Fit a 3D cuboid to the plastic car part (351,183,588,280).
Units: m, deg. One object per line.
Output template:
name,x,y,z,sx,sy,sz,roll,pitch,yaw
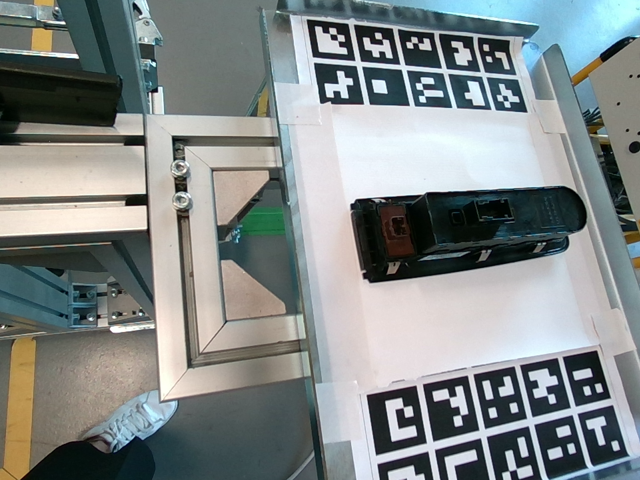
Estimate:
plastic car part,0.131,-0.018,0.337,0.202,0.066,0.067,-4,-21,-22
